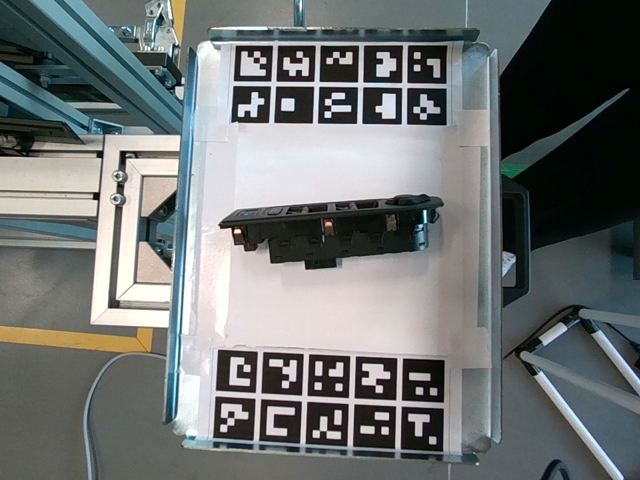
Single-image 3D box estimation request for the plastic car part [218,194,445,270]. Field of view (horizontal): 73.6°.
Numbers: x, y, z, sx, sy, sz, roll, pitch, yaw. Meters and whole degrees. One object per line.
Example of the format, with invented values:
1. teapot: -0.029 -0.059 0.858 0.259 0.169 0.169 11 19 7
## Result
1. plastic car part: 0.016 -0.009 0.393 0.203 0.067 0.066 -9 2 4
